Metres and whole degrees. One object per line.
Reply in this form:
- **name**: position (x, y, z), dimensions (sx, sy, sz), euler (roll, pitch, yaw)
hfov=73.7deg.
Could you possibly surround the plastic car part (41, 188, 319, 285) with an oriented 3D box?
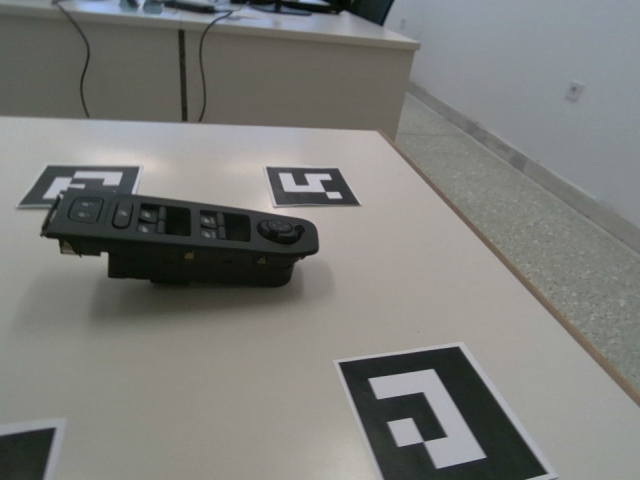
- **plastic car part**: position (-0.098, 0.005, 0.342), dimensions (0.202, 0.067, 0.066), euler (1, 26, -16)
